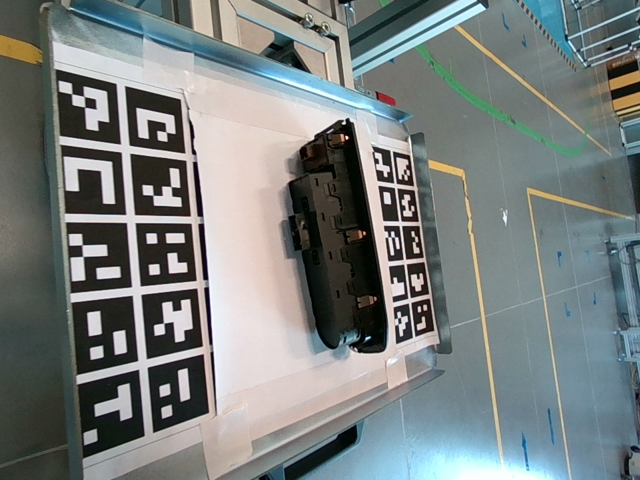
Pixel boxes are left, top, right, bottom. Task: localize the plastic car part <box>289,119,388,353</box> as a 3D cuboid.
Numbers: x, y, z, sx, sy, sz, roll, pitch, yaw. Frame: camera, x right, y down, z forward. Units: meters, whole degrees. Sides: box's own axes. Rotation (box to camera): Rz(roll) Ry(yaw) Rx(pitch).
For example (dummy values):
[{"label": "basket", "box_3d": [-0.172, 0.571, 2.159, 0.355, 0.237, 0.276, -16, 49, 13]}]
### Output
[{"label": "plastic car part", "box_3d": [0.013, 0.006, 0.366, 0.066, 0.203, 0.067, -17, 4, -35]}]
